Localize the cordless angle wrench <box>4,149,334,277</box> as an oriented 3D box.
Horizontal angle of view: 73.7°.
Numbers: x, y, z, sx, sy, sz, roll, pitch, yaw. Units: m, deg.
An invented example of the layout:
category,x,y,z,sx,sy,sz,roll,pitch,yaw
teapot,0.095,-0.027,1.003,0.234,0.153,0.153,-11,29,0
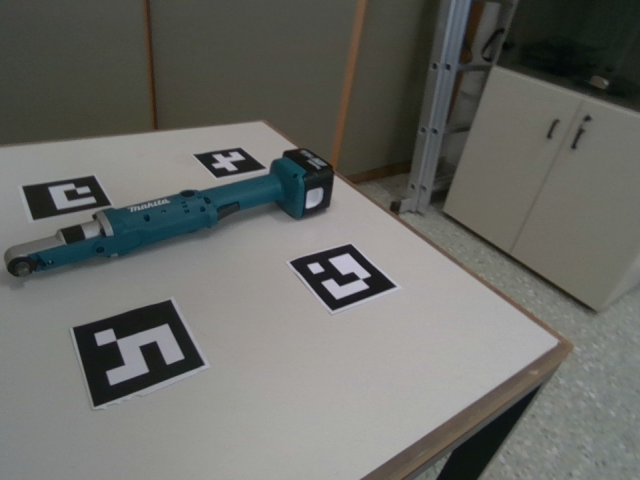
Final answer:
category,x,y,z,sx,sy,sz,roll,pitch,yaw
cordless angle wrench,-0.172,-0.037,0.569,0.419,0.074,0.099,-20,44,-31
